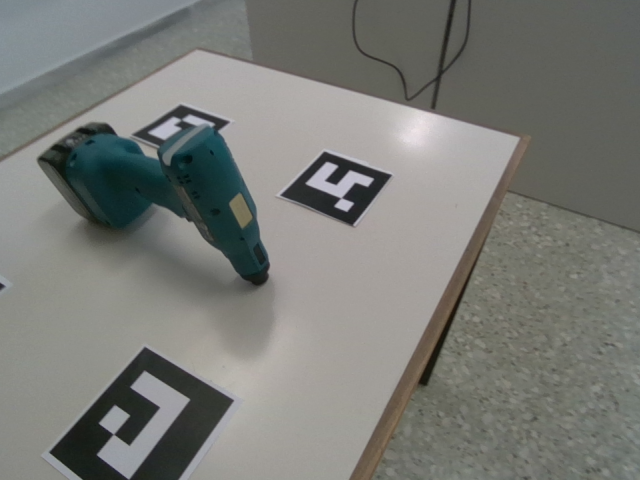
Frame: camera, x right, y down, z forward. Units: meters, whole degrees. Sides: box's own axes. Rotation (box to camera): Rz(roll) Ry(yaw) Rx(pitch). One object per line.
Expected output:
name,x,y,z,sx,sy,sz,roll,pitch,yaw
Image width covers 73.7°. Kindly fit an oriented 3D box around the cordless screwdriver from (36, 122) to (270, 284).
cordless screwdriver,-0.161,-0.038,0.427,0.251,0.158,0.074,13,50,34
